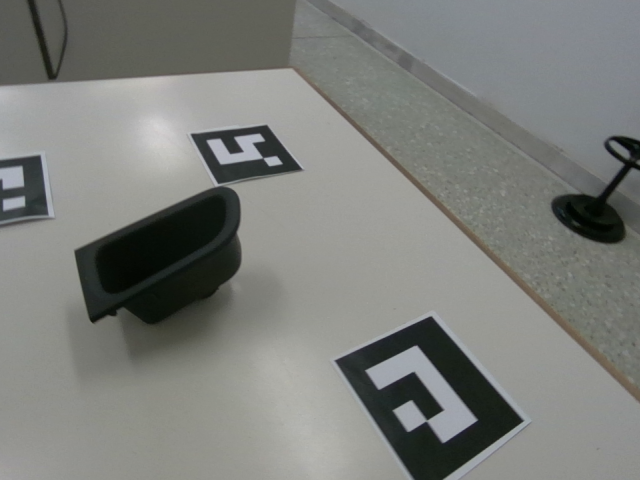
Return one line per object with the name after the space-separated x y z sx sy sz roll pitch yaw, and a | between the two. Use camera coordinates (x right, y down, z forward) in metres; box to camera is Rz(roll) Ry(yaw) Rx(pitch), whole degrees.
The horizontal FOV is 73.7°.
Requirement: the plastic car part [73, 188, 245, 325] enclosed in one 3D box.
-0.101 0.020 0.310 0.116 0.066 0.071 -26 -37 -15 | plastic car part
